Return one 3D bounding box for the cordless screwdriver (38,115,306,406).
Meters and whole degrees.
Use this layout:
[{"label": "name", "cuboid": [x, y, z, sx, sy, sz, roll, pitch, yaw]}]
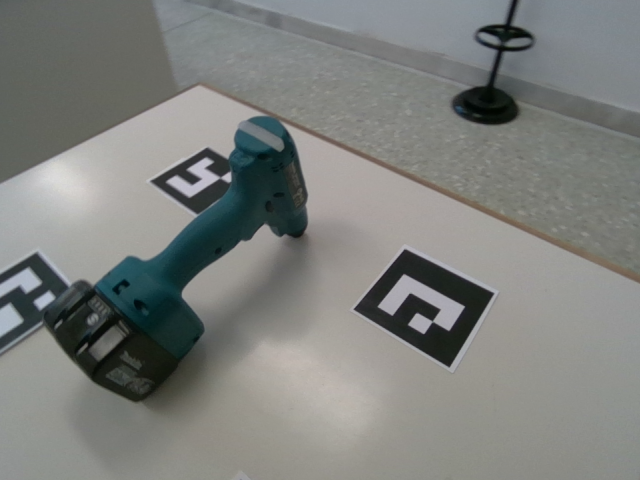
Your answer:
[{"label": "cordless screwdriver", "cuboid": [-0.100, 0.023, 0.384, 0.075, 0.247, 0.159, 32, -20, 24]}]
